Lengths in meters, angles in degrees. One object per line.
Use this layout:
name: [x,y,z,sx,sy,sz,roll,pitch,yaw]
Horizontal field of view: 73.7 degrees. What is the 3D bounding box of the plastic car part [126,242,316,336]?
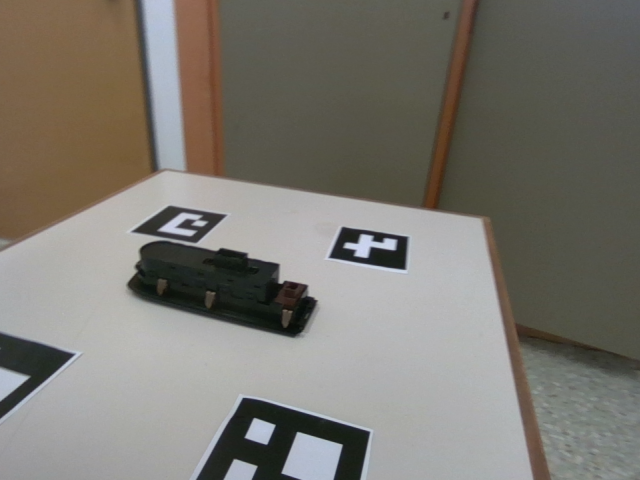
plastic car part: [-0.109,0.042,0.438,0.204,0.067,0.066,7,33,14]
